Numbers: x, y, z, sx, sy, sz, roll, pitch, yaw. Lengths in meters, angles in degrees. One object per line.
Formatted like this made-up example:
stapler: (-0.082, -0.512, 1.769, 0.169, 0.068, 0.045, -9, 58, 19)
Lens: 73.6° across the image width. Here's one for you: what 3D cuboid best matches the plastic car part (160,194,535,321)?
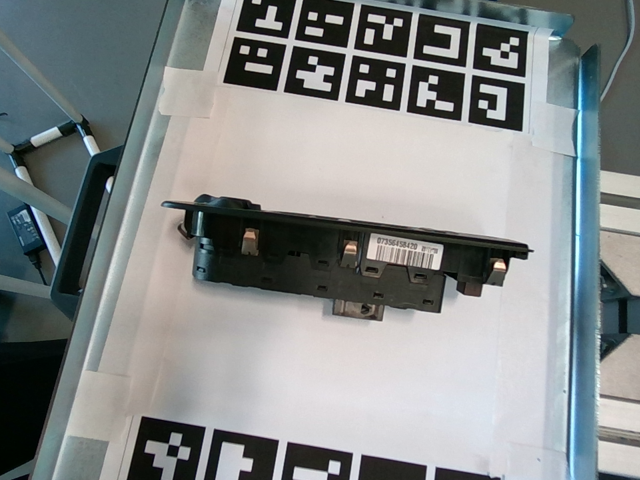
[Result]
plastic car part: (0.009, 0.010, 0.257, 0.203, 0.067, 0.066, 12, 12, -1)
